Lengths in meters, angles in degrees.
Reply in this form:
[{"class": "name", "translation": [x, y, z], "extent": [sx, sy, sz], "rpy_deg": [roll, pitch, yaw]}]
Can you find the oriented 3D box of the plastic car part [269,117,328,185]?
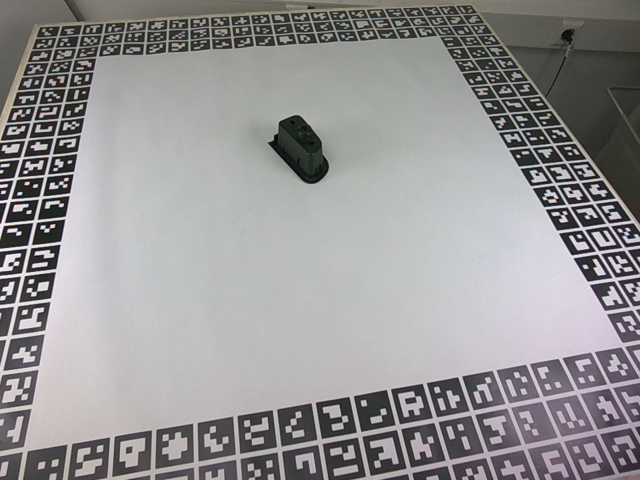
[{"class": "plastic car part", "translation": [-0.028, -0.152, 0.675], "extent": [0.066, 0.117, 0.071], "rpy_deg": [-26, -34, -18]}]
